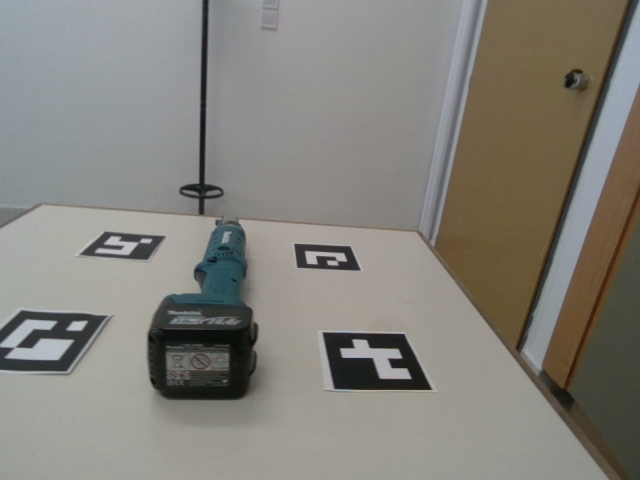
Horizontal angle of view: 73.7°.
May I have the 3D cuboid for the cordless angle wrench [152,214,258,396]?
[{"bbox_3d":[-0.135,0.038,0.584,0.097,0.074,0.424,4,20,-9],"label":"cordless angle wrench"}]
